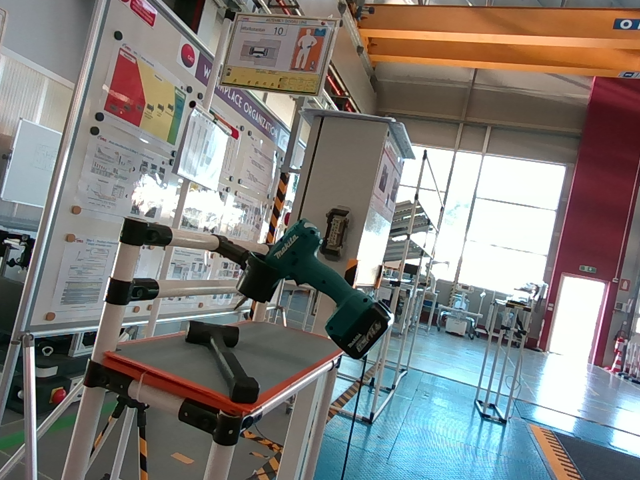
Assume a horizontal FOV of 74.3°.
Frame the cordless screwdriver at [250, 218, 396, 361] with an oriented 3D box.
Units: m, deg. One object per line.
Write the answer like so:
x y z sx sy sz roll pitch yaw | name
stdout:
-0.002 0.099 0.724 0.248 0.159 0.074 47 11 16 | cordless screwdriver
